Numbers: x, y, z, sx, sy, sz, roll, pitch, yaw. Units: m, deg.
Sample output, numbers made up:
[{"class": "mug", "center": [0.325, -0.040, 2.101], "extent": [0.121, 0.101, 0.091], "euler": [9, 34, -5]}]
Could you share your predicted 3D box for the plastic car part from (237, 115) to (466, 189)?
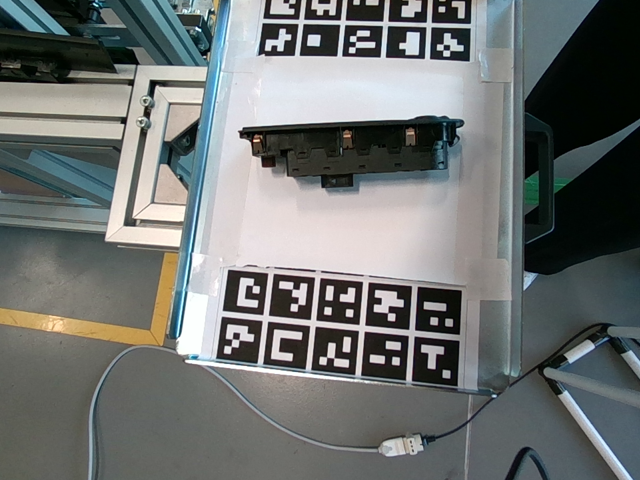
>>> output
[{"class": "plastic car part", "center": [0.032, -0.082, 0.392], "extent": [0.203, 0.067, 0.066], "euler": [-6, -2, 6]}]
